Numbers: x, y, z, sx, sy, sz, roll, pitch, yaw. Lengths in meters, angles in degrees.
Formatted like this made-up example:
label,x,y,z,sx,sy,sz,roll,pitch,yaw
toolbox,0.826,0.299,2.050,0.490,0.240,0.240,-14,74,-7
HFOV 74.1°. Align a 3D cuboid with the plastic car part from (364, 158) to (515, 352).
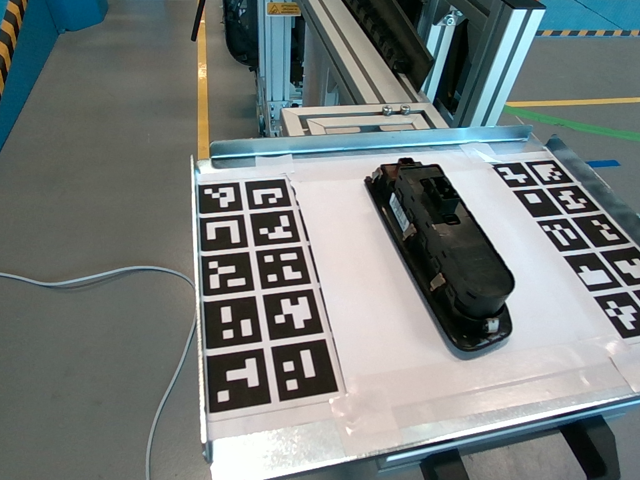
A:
label,x,y,z,sx,sy,sz,roll,pitch,yaw
plastic car part,0.104,-0.007,0.359,0.066,0.203,0.067,-3,-38,-18
